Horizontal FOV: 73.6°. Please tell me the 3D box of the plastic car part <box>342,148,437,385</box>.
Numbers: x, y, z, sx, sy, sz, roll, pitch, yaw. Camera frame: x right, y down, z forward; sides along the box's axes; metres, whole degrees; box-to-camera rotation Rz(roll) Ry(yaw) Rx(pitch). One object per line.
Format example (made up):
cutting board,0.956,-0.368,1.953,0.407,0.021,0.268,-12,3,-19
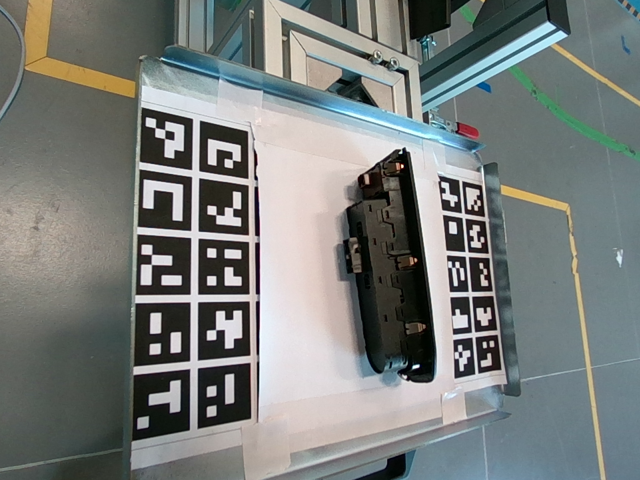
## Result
plastic car part,0.058,0.029,0.369,0.067,0.203,0.067,-10,-3,-24
